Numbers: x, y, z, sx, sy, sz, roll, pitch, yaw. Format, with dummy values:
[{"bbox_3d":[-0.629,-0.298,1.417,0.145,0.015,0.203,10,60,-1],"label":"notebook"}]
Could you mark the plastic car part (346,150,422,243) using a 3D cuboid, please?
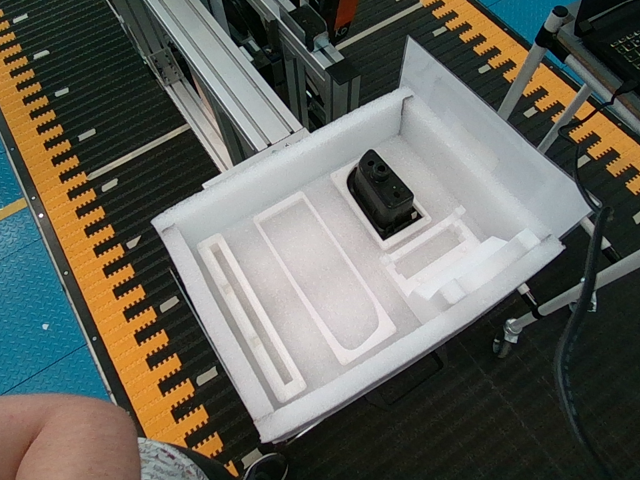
[{"bbox_3d":[0.079,-0.067,0.554,0.066,0.116,0.071,-29,-18,-13],"label":"plastic car part"}]
